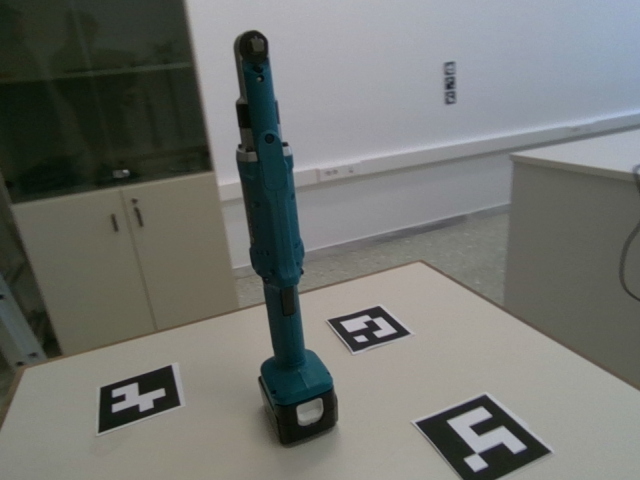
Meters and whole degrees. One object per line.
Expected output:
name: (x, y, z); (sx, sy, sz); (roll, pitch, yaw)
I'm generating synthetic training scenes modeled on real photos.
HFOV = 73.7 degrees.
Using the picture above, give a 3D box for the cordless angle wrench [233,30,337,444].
cordless angle wrench: (-0.045, 0.015, 0.446); (0.074, 0.422, 0.099); (-13, 22, -19)
